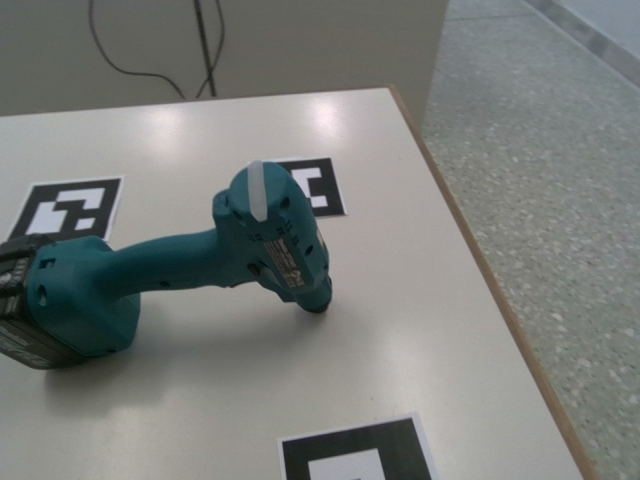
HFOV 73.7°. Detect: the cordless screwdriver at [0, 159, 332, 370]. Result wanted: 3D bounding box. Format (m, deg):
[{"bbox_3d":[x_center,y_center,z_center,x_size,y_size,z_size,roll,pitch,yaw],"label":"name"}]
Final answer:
[{"bbox_3d":[-0.115,0.037,0.337,0.249,0.074,0.158,-16,-38,6],"label":"cordless screwdriver"}]
